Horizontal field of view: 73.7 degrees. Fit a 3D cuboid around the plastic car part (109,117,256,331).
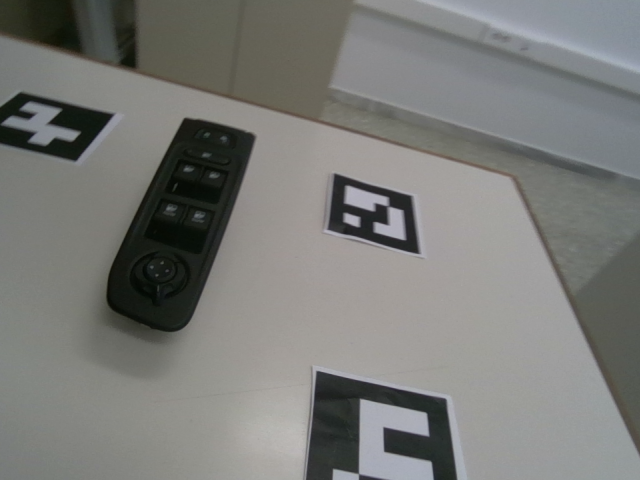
[{"bbox_3d":[-0.107,-0.015,0.340,0.066,0.203,0.067,19,-45,-14],"label":"plastic car part"}]
